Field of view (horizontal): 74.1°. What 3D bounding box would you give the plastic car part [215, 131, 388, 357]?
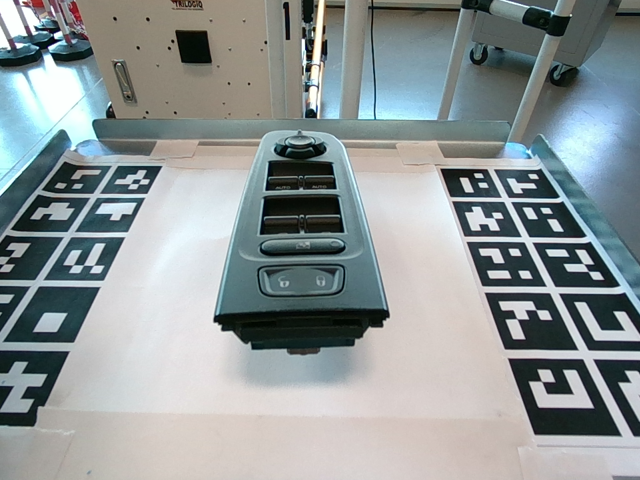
[{"bbox_3d":[-0.008,-0.009,0.252,0.066,0.067,0.202,-8,39,3],"label":"plastic car part"}]
